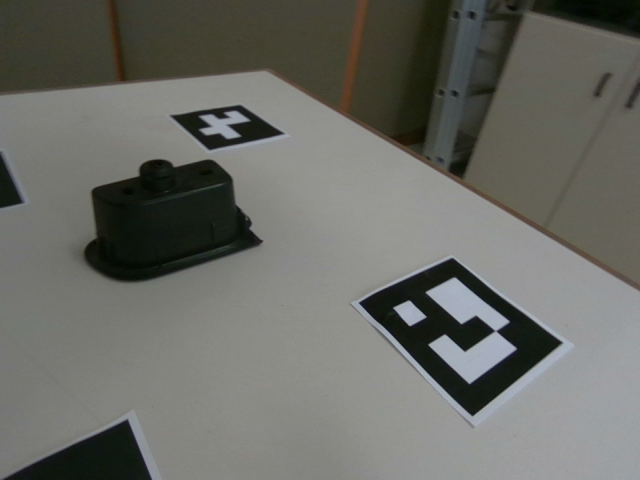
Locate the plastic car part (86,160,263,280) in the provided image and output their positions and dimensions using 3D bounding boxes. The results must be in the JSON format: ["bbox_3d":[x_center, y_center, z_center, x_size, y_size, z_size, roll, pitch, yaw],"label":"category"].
[{"bbox_3d":[-0.106,-0.022,0.304,0.115,0.071,0.066,-18,42,-35],"label":"plastic car part"}]
